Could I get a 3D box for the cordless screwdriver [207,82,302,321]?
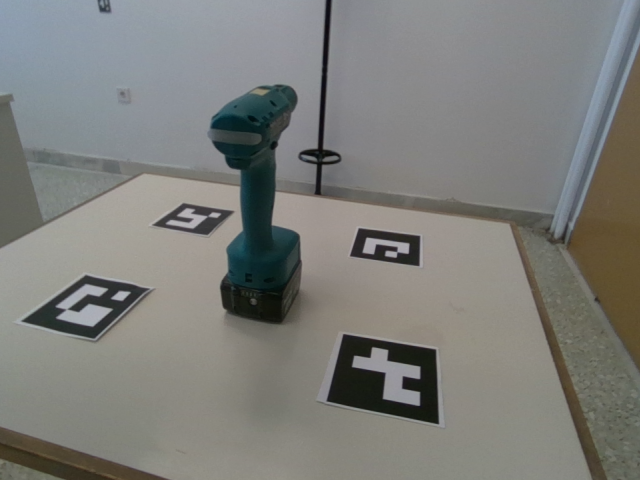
[{"bbox_3d":[-0.058,-0.043,0.477,0.075,0.249,0.158,10,33,12],"label":"cordless screwdriver"}]
